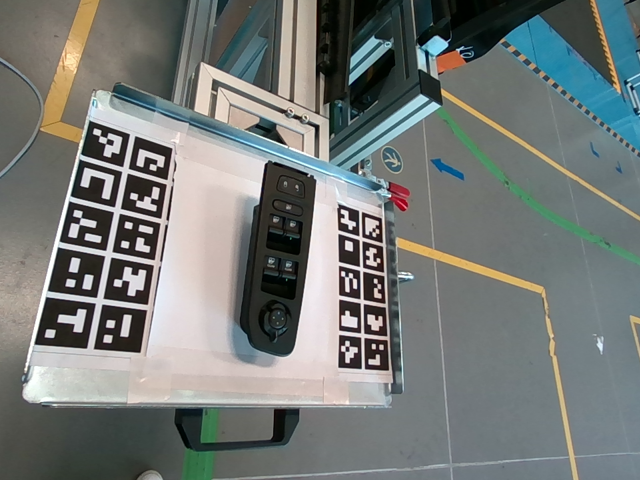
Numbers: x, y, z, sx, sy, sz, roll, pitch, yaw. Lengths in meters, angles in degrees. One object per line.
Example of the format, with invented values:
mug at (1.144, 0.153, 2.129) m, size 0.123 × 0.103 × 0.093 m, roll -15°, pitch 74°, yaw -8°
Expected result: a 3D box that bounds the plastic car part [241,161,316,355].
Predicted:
plastic car part at (-0.054, 0.021, 0.468) m, size 0.066 × 0.202 × 0.067 m, roll 17°, pitch -22°, yaw -40°
